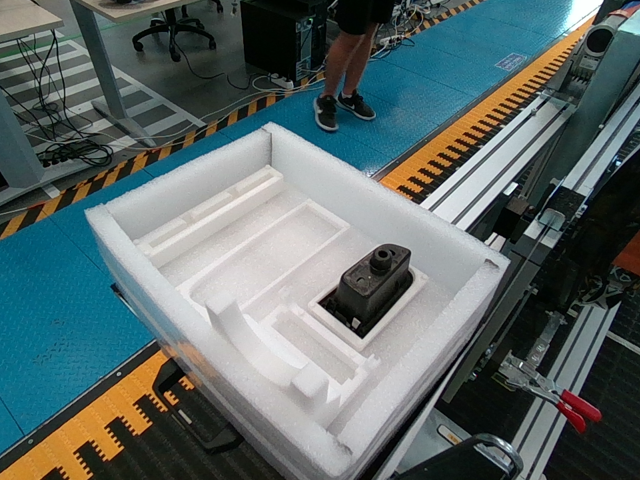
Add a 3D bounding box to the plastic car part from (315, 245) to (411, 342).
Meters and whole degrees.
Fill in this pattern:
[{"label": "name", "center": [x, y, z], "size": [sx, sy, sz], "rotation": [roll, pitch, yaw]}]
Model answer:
[{"label": "plastic car part", "center": [0.059, 0.043, 0.475], "size": [0.066, 0.071, 0.116], "rotation": [36, 57, 25]}]
